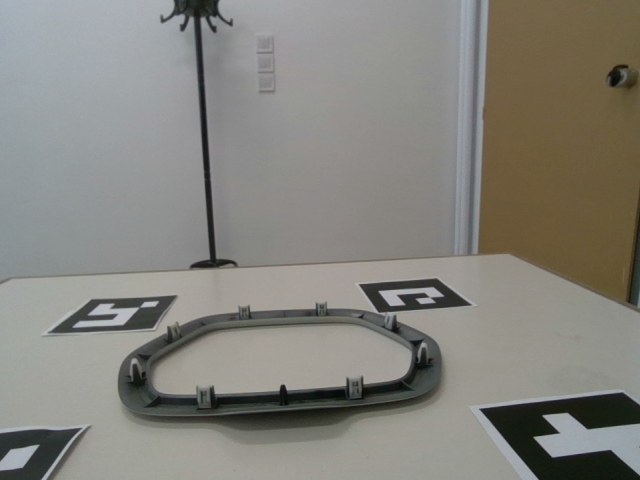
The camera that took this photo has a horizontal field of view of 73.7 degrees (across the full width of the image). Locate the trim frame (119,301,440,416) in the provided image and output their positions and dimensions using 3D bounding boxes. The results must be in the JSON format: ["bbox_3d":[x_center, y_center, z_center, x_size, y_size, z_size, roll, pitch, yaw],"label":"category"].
[{"bbox_3d":[-0.030,0.088,0.342,0.248,0.027,0.184,-1,13,-2],"label":"trim frame"}]
